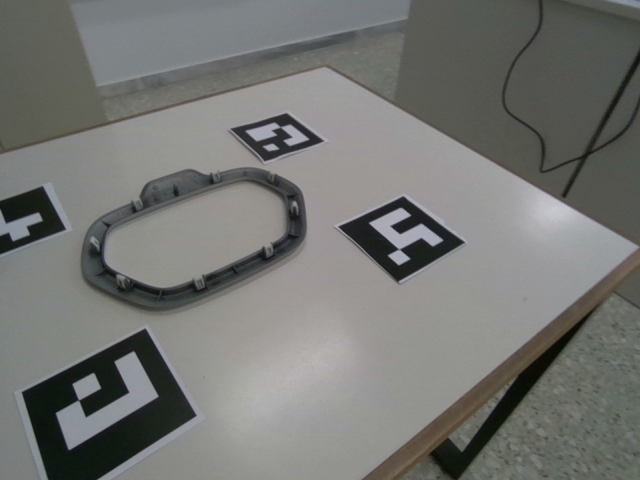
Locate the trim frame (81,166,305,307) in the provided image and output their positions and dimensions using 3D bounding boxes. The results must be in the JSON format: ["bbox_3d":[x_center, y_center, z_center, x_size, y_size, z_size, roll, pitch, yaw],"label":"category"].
[{"bbox_3d":[-0.131,-0.019,0.468,0.247,0.027,0.185,-26,50,-23],"label":"trim frame"}]
